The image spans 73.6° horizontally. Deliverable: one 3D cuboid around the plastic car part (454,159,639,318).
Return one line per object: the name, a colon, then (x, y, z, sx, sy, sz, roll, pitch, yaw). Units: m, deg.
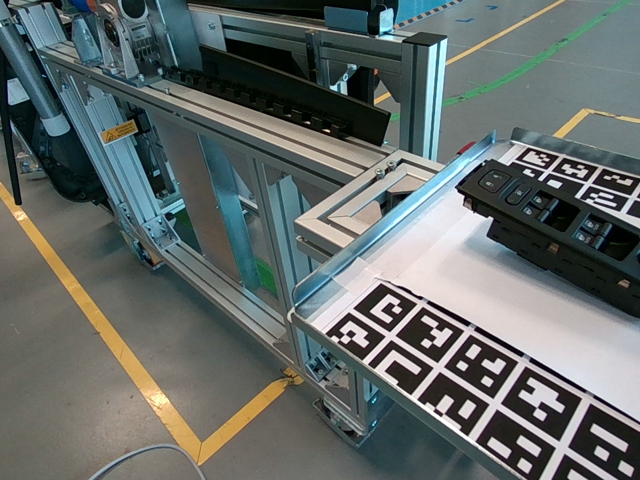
plastic car part: (0.214, 0.003, 0.367, 0.204, 0.067, 0.066, 33, 47, 32)
